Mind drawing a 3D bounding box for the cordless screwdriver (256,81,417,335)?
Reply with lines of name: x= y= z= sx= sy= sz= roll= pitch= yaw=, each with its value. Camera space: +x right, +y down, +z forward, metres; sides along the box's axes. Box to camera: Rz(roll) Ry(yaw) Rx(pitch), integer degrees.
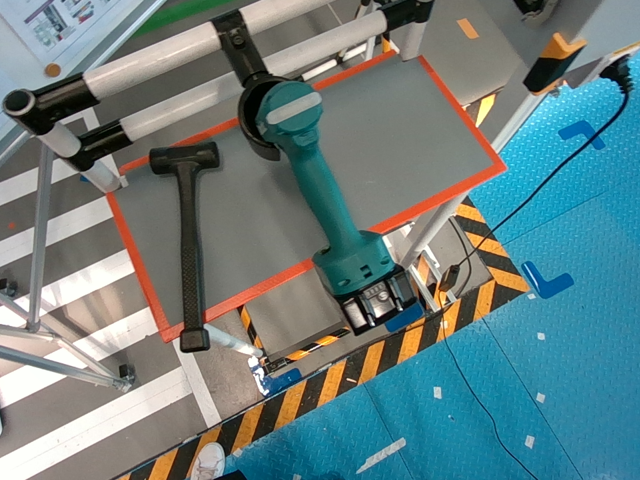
cordless screwdriver: x=0.005 y=-0.034 z=0.446 sx=0.074 sy=0.249 sz=0.159 roll=-27 pitch=14 yaw=-7
